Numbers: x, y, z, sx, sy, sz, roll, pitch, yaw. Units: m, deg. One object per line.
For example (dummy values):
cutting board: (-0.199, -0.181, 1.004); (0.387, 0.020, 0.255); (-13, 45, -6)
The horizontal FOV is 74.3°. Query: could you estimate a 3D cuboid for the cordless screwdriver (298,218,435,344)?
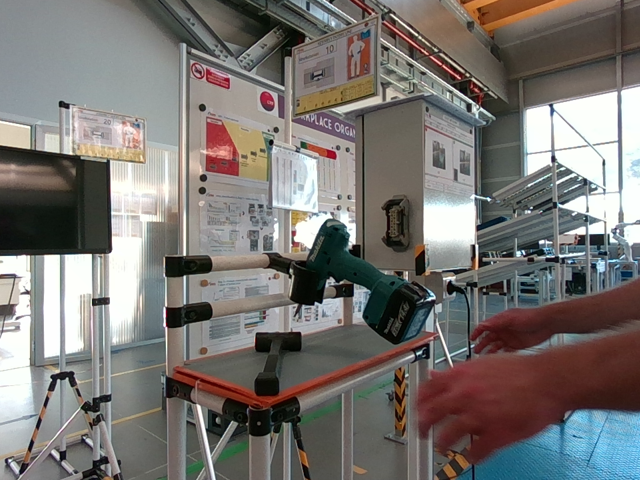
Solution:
cordless screwdriver: (0.064, 0.088, 0.744); (0.248, 0.159, 0.074); (38, 21, 33)
